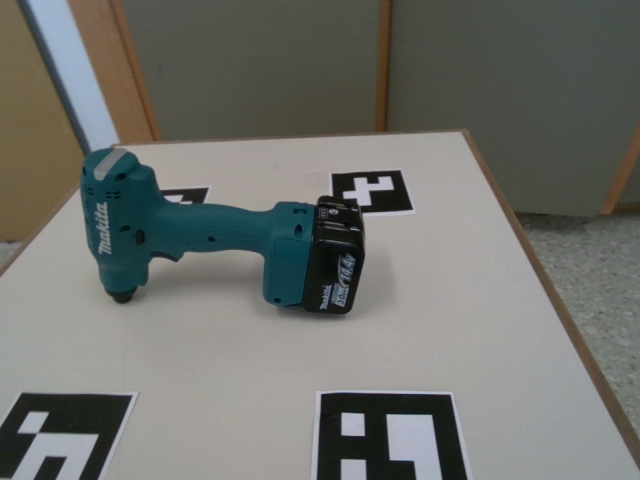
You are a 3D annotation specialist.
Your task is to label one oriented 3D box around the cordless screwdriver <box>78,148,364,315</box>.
[{"bbox_3d":[-0.090,0.016,0.397,0.248,0.159,0.074,11,35,-3],"label":"cordless screwdriver"}]
